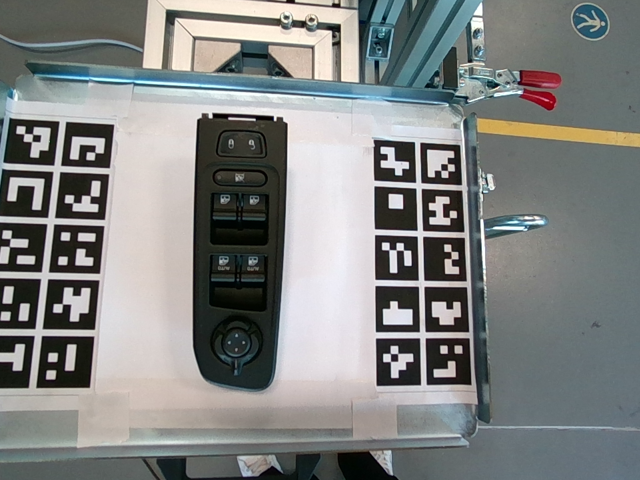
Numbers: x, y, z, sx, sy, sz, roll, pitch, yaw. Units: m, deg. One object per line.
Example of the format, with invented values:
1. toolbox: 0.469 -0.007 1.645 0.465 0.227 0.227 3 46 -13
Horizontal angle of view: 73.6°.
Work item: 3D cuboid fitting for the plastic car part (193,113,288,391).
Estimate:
1. plastic car part: -0.064 0.011 0.330 0.066 0.202 0.067 2 -6 -14
